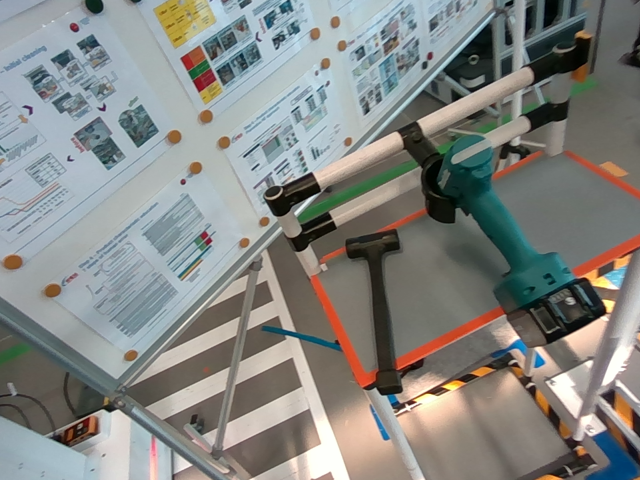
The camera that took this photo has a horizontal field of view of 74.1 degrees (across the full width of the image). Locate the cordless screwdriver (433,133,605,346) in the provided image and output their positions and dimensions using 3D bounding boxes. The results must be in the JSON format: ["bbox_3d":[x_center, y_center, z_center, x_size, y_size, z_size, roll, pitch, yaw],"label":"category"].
[{"bbox_3d":[0.217,0.001,0.521,0.074,0.248,0.159,-27,-14,1],"label":"cordless screwdriver"}]
